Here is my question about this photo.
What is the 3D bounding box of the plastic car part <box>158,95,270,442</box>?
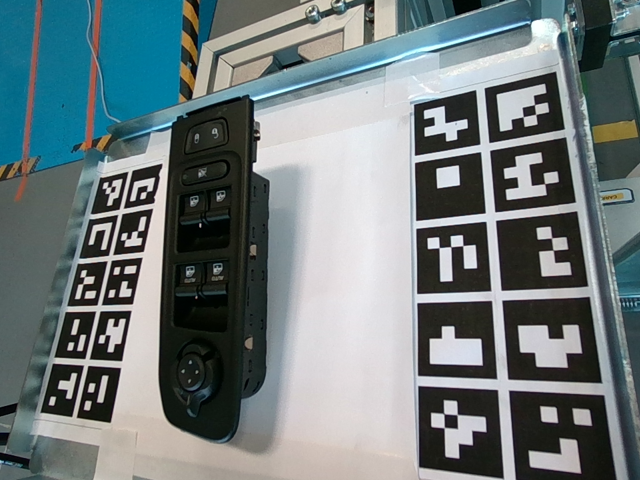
[{"bbox_3d":[-0.063,0.016,0.274,0.066,0.202,0.067,-4,-17,18],"label":"plastic car part"}]
